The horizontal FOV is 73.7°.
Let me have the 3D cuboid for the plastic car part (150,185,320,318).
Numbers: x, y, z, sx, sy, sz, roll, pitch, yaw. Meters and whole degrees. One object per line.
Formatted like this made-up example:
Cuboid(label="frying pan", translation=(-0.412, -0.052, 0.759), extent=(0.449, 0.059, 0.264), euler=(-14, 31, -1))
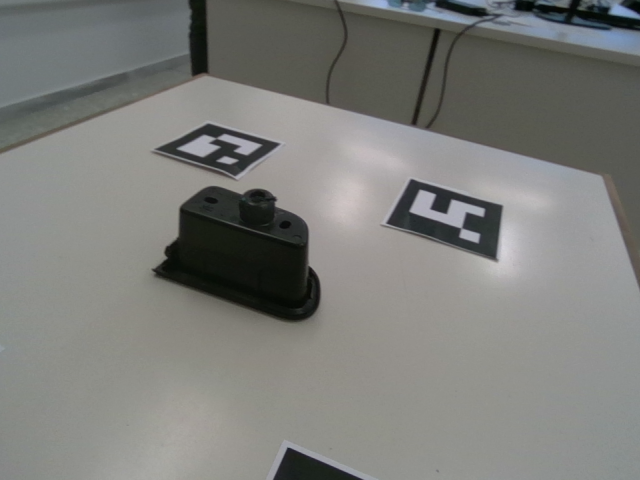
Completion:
Cuboid(label="plastic car part", translation=(-0.050, -0.001, 0.291), extent=(0.117, 0.071, 0.065), euler=(16, 39, 12))
